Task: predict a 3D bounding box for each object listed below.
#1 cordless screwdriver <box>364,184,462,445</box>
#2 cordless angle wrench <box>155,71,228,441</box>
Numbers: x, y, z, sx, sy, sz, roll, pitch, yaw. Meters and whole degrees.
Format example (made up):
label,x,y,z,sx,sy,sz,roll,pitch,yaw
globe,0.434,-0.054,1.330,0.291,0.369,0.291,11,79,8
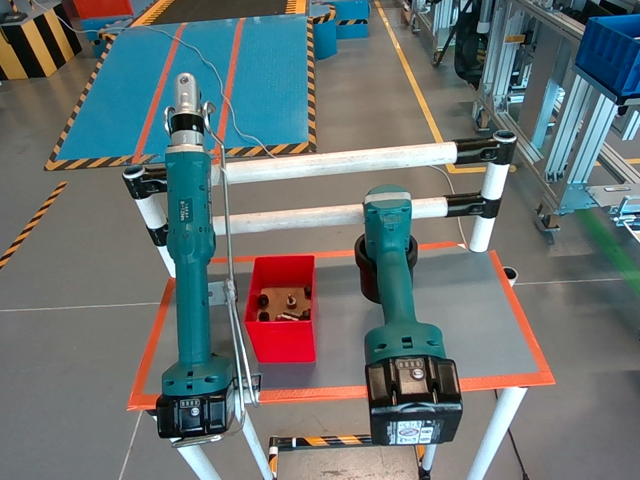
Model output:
label,x,y,z,sx,sy,sz,roll,pitch,yaw
cordless screwdriver,0.081,0.080,0.446,0.074,0.248,0.159,-4,-39,5
cordless angle wrench,-0.155,0.004,0.500,0.074,0.422,0.098,-3,-6,-12
